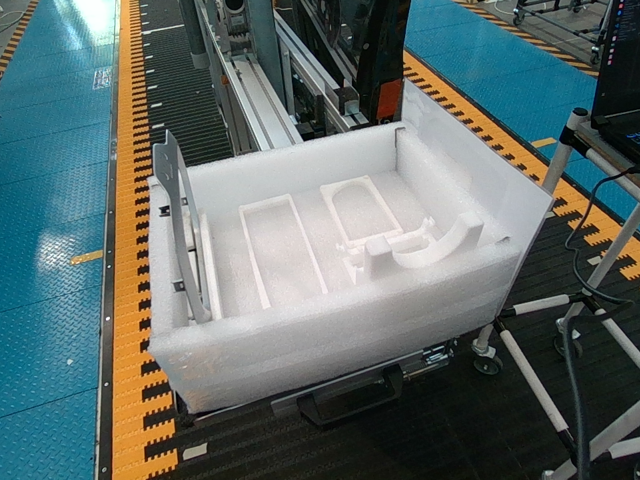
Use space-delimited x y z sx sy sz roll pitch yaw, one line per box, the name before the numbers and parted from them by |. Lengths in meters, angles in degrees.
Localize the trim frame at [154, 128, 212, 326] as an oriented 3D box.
trim frame | -0.152 -0.016 0.477 0.027 0.248 0.184 -10 -42 -10
